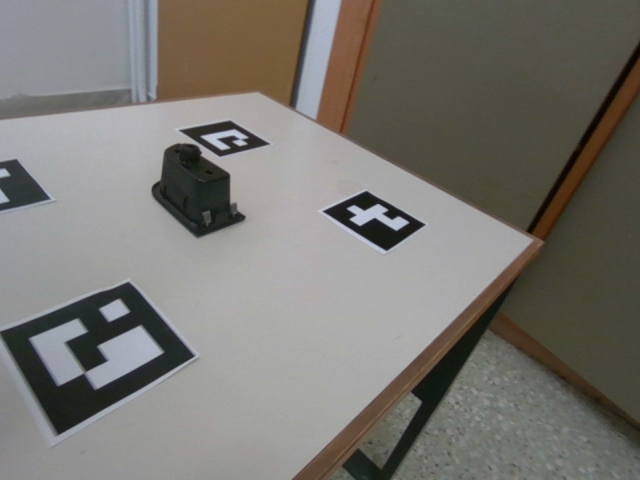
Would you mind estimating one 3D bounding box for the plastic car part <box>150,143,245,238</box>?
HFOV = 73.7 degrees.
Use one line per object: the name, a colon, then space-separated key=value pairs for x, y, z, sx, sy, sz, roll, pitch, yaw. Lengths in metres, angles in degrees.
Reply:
plastic car part: x=-0.139 y=-0.066 z=0.463 sx=0.117 sy=0.071 sz=0.065 roll=37 pitch=39 yaw=25
